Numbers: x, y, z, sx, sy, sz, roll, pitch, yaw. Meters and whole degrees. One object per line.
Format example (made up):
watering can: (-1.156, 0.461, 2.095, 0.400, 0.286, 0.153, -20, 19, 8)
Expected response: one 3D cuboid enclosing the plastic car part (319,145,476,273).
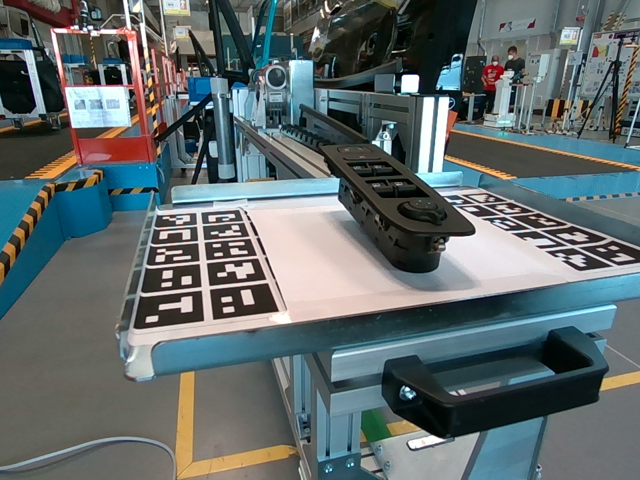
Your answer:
plastic car part: (0.055, -0.033, 0.380, 0.066, 0.067, 0.203, 1, 24, -19)
